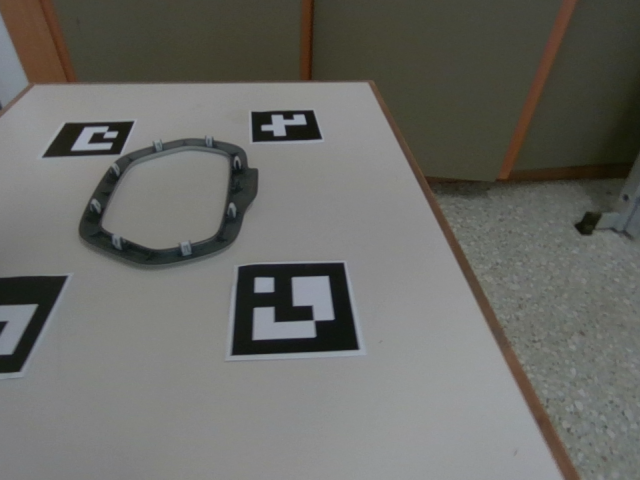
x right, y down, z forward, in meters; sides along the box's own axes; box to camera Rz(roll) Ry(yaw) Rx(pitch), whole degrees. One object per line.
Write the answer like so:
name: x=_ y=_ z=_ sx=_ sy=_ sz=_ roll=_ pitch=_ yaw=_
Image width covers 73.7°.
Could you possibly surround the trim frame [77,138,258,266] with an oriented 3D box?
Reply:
trim frame: x=-0.162 y=-0.058 z=0.483 sx=0.184 sy=0.027 sz=0.249 roll=-2 pitch=38 yaw=-5
